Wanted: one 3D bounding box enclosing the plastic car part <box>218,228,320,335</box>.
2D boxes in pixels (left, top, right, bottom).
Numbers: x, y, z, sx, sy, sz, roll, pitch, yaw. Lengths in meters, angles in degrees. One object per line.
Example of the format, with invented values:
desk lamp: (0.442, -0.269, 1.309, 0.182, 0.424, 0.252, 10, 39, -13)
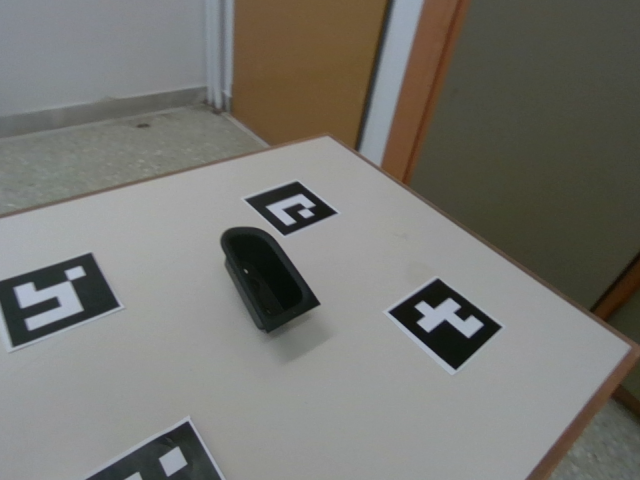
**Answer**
plastic car part: (-0.066, 0.048, 0.457, 0.065, 0.117, 0.071, -23, -24, -32)
